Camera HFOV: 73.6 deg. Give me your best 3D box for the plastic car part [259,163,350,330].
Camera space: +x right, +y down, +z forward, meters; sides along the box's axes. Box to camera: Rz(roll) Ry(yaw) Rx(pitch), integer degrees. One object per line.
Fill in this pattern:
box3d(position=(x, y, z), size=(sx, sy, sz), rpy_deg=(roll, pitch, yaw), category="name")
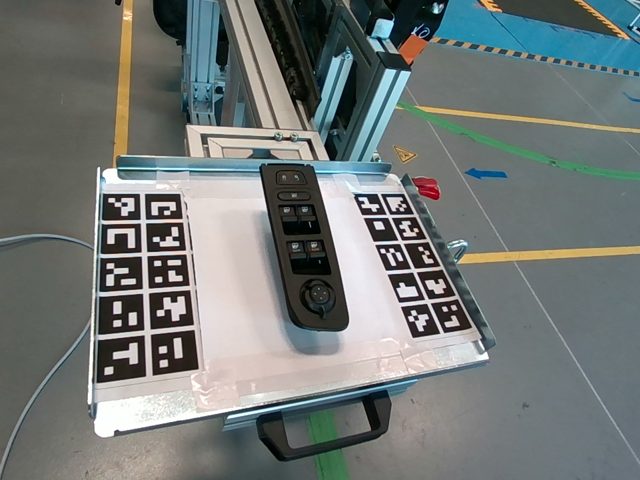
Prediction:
box3d(position=(-0.024, 0.010, 0.465), size=(0.066, 0.203, 0.067), rpy_deg=(1, -35, -28), category="plastic car part")
